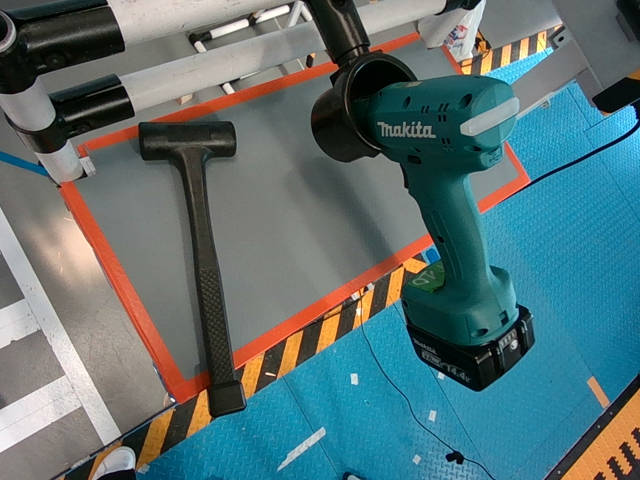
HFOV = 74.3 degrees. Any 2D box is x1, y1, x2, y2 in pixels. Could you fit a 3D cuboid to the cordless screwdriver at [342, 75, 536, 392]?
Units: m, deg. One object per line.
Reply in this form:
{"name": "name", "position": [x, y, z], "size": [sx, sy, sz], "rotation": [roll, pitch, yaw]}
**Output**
{"name": "cordless screwdriver", "position": [0.092, -0.006, 0.359], "size": [0.074, 0.249, 0.159], "rotation": [-29, 27, -23]}
